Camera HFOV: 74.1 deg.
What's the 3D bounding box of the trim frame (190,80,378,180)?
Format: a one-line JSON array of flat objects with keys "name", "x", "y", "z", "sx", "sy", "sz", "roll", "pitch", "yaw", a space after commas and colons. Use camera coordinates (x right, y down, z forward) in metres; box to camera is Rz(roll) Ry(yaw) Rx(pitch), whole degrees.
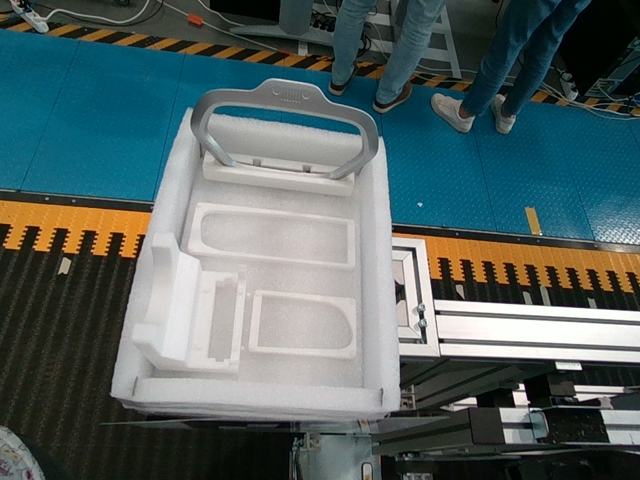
[{"name": "trim frame", "x": -0.046, "y": -0.136, "z": 0.565, "sx": 0.248, "sy": 0.027, "sz": 0.185, "roll": 7, "pitch": -24, "yaw": -5}]
